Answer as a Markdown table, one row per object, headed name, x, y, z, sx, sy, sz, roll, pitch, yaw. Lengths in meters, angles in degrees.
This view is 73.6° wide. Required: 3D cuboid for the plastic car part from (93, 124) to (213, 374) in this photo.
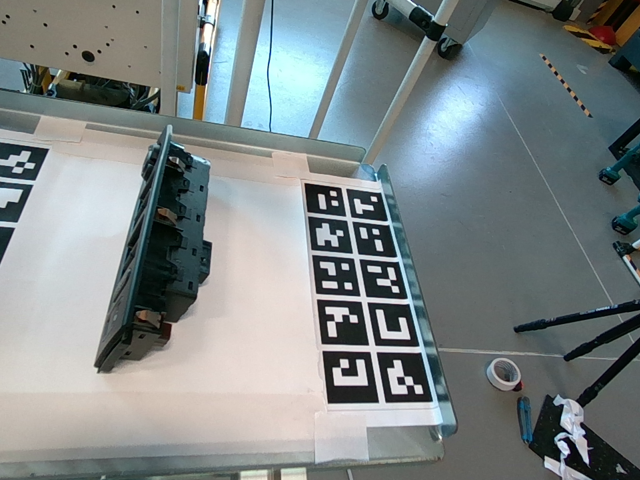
| name | x | y | z | sx | sy | sz | roll | pitch | yaw |
| --- | --- | --- | --- | --- | --- | --- | --- | --- | --- |
| plastic car part | -0.114 | -0.007 | 0.320 | 0.067 | 0.202 | 0.067 | 11 | -39 | -26 |
